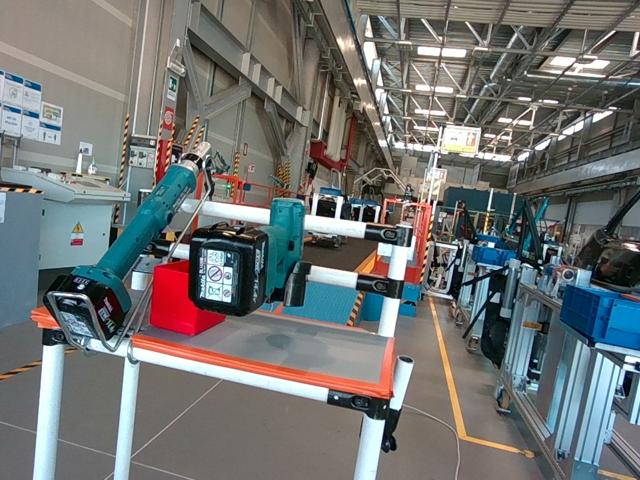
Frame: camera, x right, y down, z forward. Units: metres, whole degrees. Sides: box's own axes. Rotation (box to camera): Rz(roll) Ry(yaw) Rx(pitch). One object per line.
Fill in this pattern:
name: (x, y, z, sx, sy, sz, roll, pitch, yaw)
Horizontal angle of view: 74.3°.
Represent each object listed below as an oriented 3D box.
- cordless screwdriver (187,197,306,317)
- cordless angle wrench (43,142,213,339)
cordless screwdriver: (-0.075, 0.035, 0.548, 0.074, 0.159, 0.248, 6, 13, 13)
cordless angle wrench: (-0.276, -0.039, 0.706, 0.074, 0.421, 0.098, 13, -41, 7)
